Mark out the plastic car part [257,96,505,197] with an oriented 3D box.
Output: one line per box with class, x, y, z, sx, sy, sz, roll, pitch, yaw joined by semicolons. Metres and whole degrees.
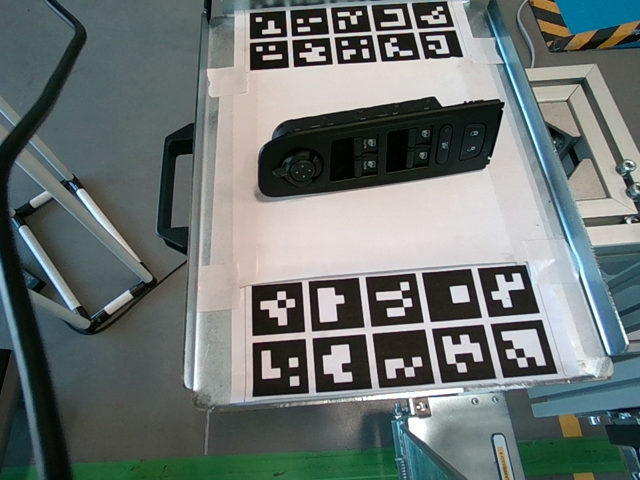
plastic car part;0.043;-0.085;0.361;0.203;0.067;0.066;-13;-36;-6
